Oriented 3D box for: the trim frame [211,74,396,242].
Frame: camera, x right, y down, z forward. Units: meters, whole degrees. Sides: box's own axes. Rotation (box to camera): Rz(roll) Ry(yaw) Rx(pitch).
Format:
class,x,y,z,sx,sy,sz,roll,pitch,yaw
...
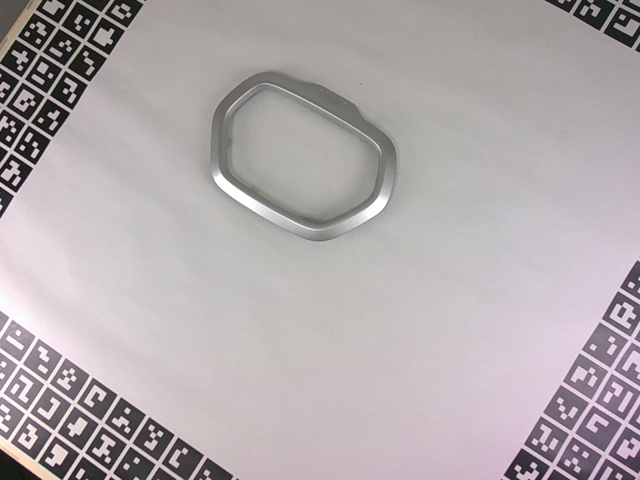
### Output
class,x,y,z,sx,sy,sz,roll,pitch,yaw
trim frame,-0.025,-0.107,0.534,0.249,0.184,0.027,30,0,9
